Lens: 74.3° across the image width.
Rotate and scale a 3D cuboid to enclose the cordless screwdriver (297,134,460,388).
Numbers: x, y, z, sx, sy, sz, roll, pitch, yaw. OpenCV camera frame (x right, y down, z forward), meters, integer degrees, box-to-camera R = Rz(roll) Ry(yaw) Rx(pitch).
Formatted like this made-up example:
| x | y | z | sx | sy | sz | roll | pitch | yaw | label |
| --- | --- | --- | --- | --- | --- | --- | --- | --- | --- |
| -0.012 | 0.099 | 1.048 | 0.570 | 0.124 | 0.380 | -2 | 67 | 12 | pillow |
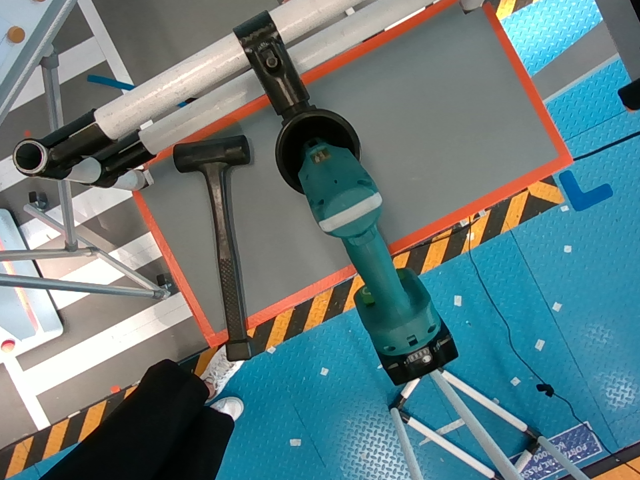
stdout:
| x | y | z | sx | sy | sz | roll | pitch | yaw | label |
| --- | --- | --- | --- | --- | --- | --- | --- | --- | --- |
| 0.048 | 0.016 | 0.413 | 0.074 | 0.249 | 0.159 | -27 | 32 | 3 | cordless screwdriver |
